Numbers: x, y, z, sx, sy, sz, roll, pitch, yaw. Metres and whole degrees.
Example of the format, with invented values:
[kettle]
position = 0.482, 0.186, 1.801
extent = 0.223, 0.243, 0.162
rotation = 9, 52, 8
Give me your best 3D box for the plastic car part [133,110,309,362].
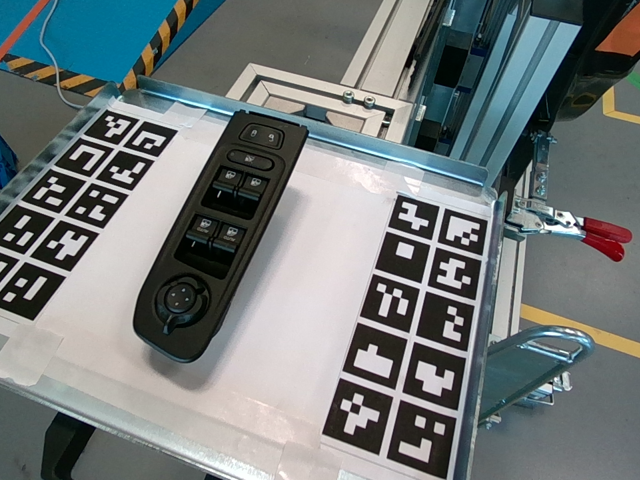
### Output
[plastic car part]
position = -0.074, -0.006, 0.331
extent = 0.066, 0.202, 0.067
rotation = 20, -28, 1
